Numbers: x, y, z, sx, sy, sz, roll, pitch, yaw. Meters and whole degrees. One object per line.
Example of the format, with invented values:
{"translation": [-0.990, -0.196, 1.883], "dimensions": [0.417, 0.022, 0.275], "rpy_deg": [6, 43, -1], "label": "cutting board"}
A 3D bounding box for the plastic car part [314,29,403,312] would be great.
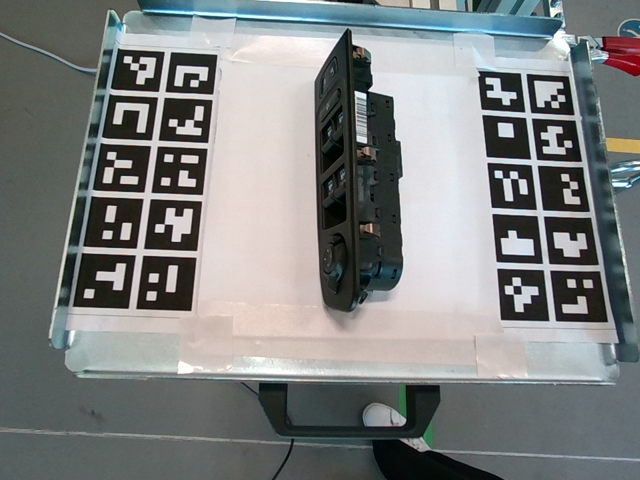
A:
{"translation": [0.028, -0.046, 0.320], "dimensions": [0.067, 0.203, 0.067], "rpy_deg": [12, -19, -28], "label": "plastic car part"}
